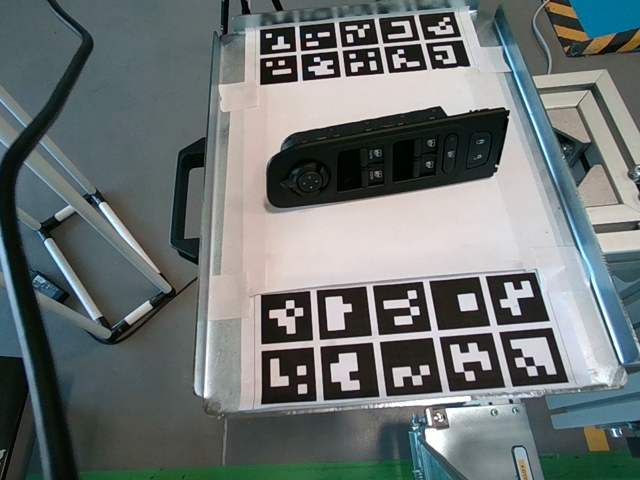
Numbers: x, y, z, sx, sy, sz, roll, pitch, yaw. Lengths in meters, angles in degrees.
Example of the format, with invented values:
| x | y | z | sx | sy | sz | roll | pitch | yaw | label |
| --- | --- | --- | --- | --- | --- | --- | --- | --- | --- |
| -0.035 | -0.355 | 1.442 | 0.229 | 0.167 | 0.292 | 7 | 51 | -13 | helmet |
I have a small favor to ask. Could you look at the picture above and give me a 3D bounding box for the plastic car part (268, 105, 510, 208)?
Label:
| x | y | z | sx | sy | sz | roll | pitch | yaw | label |
| --- | --- | --- | --- | --- | --- | --- | --- | --- | --- |
| 0.050 | -0.078 | 0.364 | 0.203 | 0.067 | 0.066 | -14 | -37 | -6 | plastic car part |
